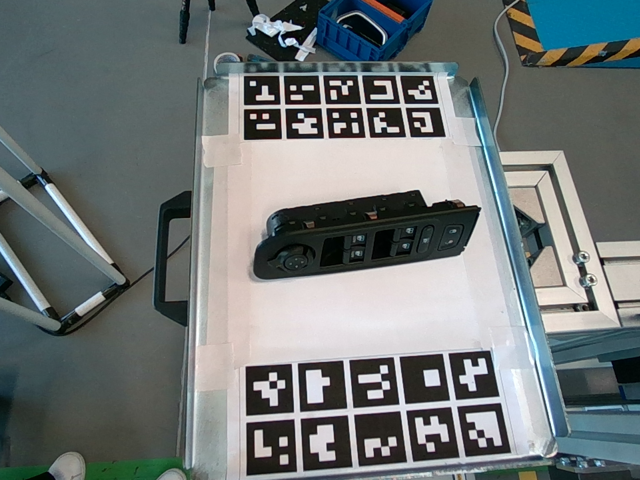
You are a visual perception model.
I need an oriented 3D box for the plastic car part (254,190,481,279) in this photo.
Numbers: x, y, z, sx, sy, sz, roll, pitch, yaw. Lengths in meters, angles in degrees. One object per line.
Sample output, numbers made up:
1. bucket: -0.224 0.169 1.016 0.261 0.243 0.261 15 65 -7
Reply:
1. plastic car part: 0.037 -0.011 0.386 0.202 0.067 0.066 -11 -31 -13
